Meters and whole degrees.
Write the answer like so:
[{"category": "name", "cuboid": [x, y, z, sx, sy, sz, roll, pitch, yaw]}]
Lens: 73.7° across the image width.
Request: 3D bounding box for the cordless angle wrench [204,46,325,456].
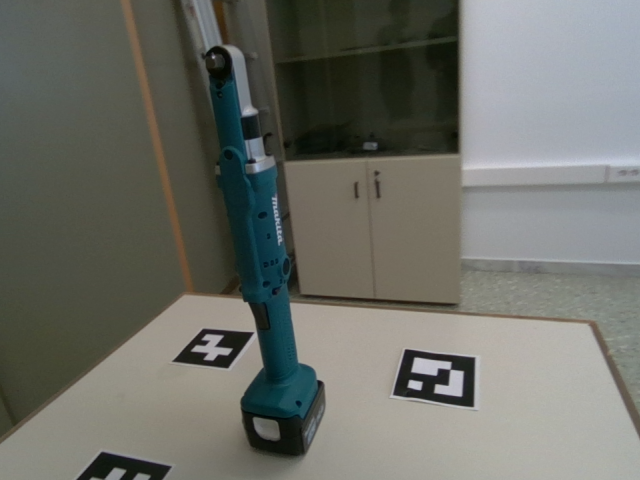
[{"category": "cordless angle wrench", "cuboid": [-0.061, 0.029, 0.443, 0.075, 0.422, 0.097, 1, 21, 20]}]
